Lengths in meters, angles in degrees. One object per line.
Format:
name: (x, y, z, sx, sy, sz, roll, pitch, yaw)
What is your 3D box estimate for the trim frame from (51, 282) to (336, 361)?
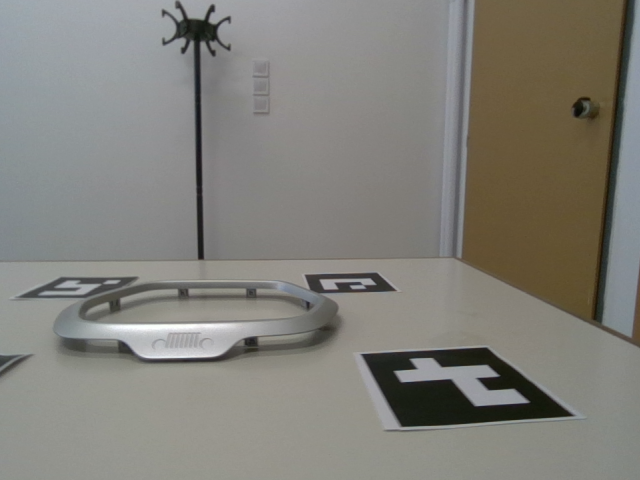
trim frame: (-0.109, 0.067, 0.395, 0.248, 0.027, 0.184, 2, 6, -5)
